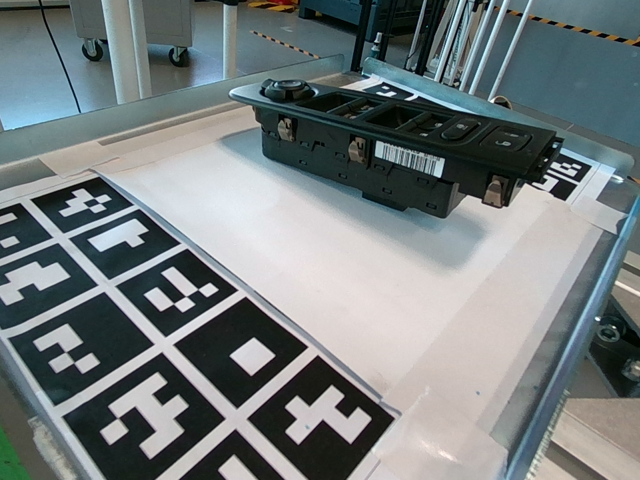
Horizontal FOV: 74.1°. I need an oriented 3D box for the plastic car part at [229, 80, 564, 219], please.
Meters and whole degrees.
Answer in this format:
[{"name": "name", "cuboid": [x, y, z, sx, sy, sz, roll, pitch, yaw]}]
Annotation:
[{"name": "plastic car part", "cuboid": [0.033, -0.061, 0.270, 0.204, 0.067, 0.066, 26, 50, 24]}]
